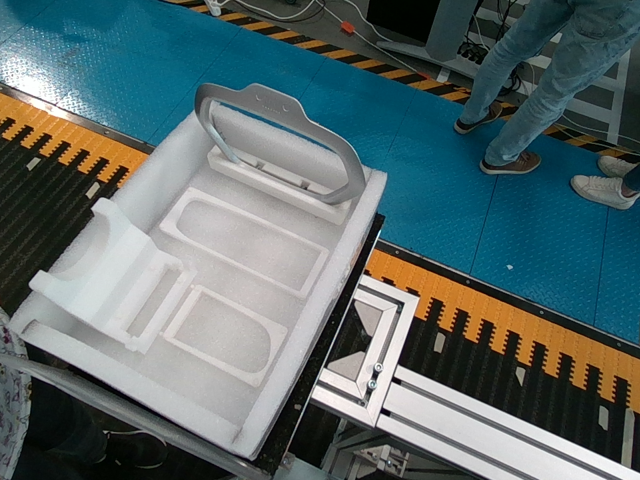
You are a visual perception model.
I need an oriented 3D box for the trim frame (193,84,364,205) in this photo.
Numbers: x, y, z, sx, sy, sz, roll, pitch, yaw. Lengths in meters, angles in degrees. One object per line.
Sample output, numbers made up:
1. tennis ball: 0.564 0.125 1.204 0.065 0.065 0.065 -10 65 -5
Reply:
1. trim frame: -0.056 -0.119 0.550 0.249 0.027 0.184 26 -23 10
